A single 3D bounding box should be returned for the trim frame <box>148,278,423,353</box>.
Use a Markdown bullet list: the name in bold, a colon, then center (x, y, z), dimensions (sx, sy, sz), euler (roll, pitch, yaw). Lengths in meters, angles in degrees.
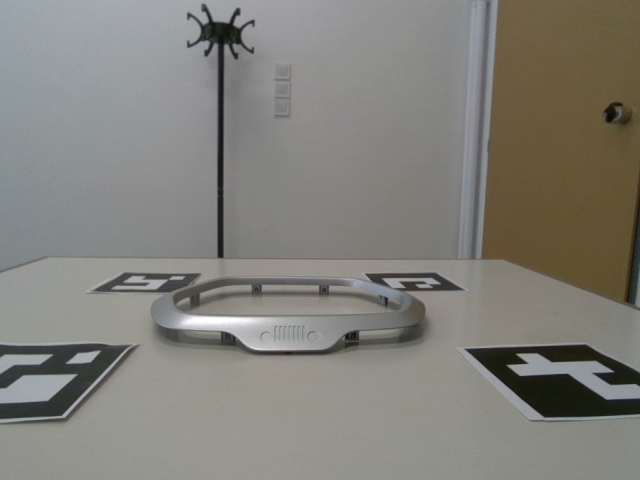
- **trim frame**: center (-0.030, 0.062, 0.395), dimensions (0.248, 0.027, 0.184), euler (2, 6, -4)
